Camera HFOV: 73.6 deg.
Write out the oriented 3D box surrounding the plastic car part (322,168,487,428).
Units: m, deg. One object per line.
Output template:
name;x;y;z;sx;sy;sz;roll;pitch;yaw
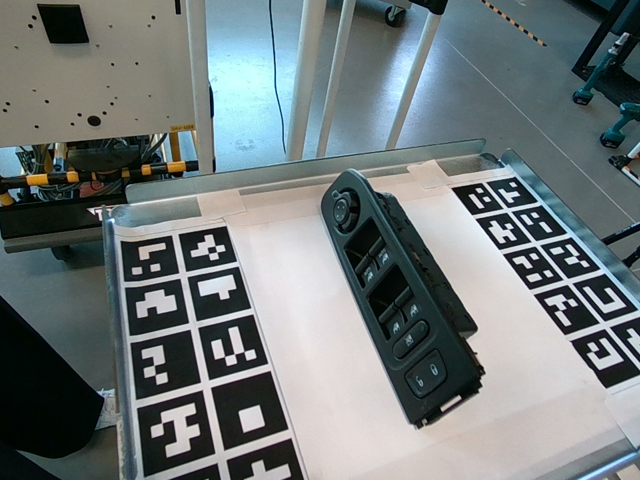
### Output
plastic car part;0.061;0.024;0.322;0.067;0.203;0.066;-6;-38;-30
